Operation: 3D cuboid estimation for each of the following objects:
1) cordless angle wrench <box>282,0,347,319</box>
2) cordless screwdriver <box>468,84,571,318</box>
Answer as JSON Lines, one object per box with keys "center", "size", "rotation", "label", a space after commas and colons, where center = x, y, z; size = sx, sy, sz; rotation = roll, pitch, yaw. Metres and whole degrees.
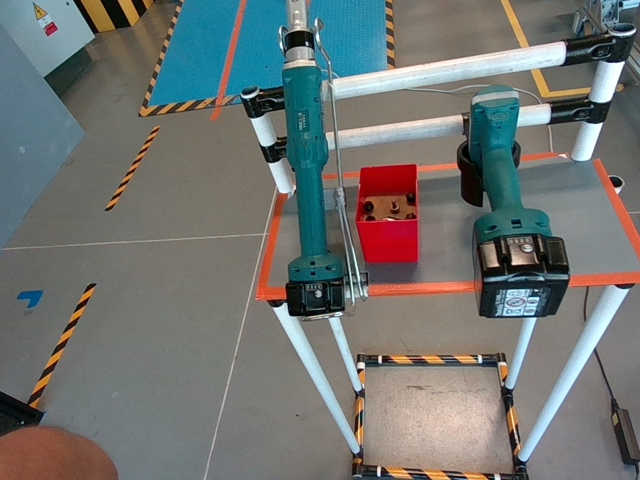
{"center": [-0.016, -0.114, 0.556], "size": [0.074, 0.422, 0.098], "rotation": [-4, -1, 5], "label": "cordless angle wrench"}
{"center": [0.202, -0.033, 0.474], "size": [0.074, 0.248, 0.159], "rotation": [-3, -32, 15], "label": "cordless screwdriver"}
